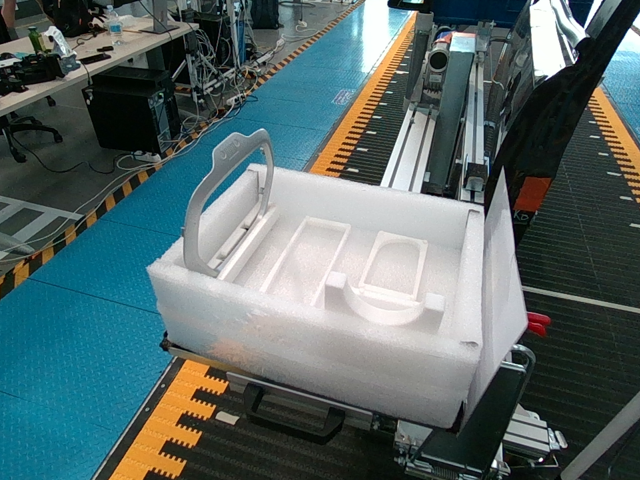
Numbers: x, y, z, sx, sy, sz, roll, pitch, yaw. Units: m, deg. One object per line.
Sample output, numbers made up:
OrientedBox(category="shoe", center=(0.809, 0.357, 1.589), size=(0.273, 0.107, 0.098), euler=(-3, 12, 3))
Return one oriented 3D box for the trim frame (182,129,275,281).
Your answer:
OrientedBox(category="trim frame", center=(-0.118, -0.053, 0.589), size=(0.027, 0.184, 0.247), euler=(19, 45, 13))
